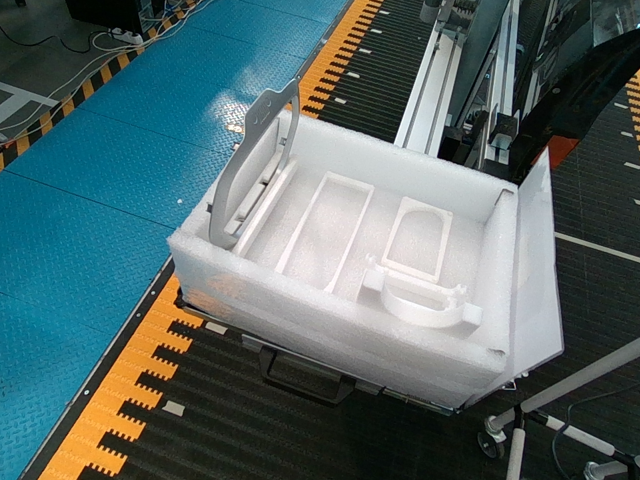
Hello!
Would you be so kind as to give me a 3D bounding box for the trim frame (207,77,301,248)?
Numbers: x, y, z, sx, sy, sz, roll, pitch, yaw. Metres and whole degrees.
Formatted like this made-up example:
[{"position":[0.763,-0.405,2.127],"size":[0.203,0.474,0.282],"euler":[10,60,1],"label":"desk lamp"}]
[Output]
[{"position":[-0.076,-0.096,0.532],"size":[0.027,0.247,0.185],"euler":[25,-33,5],"label":"trim frame"}]
